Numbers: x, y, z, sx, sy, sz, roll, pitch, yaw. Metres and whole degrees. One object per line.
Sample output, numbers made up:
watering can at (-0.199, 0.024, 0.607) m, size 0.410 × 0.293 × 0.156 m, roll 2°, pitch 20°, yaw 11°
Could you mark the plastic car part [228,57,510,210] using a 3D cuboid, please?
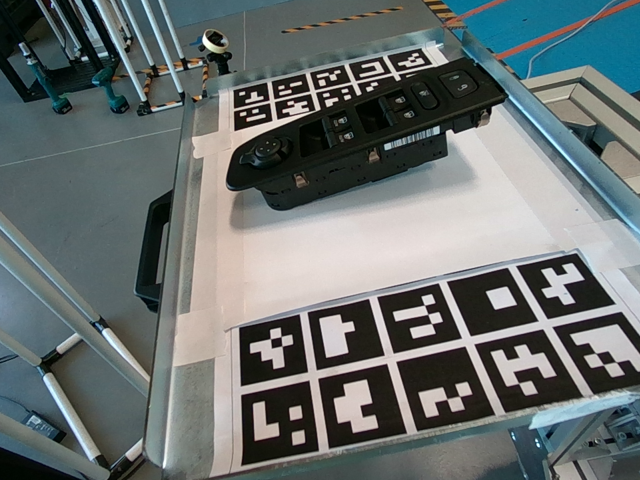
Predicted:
plastic car part at (0.029, -0.074, 0.326) m, size 0.203 × 0.066 × 0.067 m, roll -16°, pitch -35°, yaw 4°
